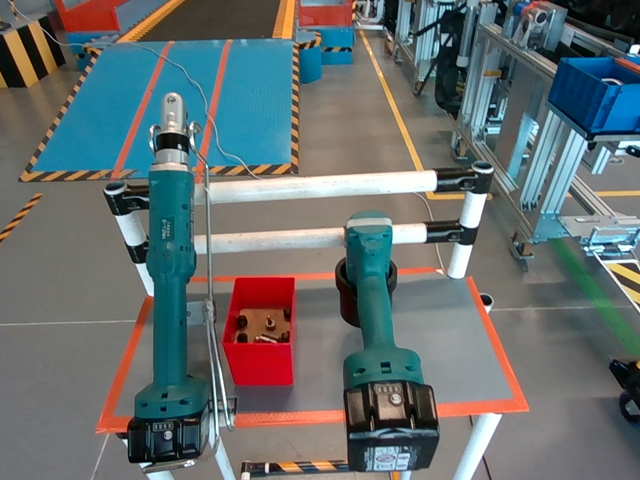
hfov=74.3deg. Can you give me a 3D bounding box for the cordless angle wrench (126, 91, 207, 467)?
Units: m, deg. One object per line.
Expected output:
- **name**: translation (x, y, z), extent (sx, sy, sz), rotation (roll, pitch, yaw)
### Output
- **cordless angle wrench**: translation (-0.174, 0.026, 0.495), extent (0.074, 0.422, 0.098), rotation (-1, -9, -11)

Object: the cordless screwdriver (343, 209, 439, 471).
- **cordless screwdriver**: translation (0.059, 0.106, 0.450), extent (0.074, 0.248, 0.160), rotation (-3, -41, 2)
